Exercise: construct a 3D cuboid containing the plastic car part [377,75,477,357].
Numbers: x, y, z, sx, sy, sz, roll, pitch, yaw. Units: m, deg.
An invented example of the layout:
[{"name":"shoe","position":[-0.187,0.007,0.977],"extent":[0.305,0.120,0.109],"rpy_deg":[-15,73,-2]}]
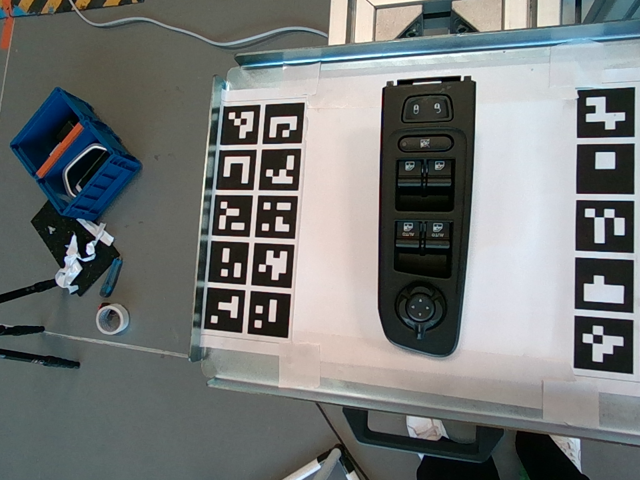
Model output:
[{"name":"plastic car part","position":[0.078,-0.015,0.332],"extent":[0.066,0.203,0.067],"rpy_deg":[2,-1,7]}]
